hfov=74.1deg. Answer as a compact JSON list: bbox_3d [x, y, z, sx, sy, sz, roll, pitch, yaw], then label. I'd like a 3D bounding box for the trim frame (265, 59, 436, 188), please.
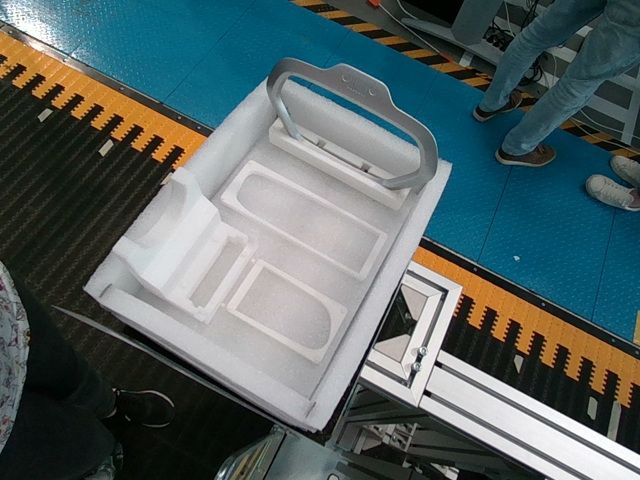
[{"bbox_3d":[0.036,-0.144,0.549,0.249,0.027,0.184,31,-19,7],"label":"trim frame"}]
